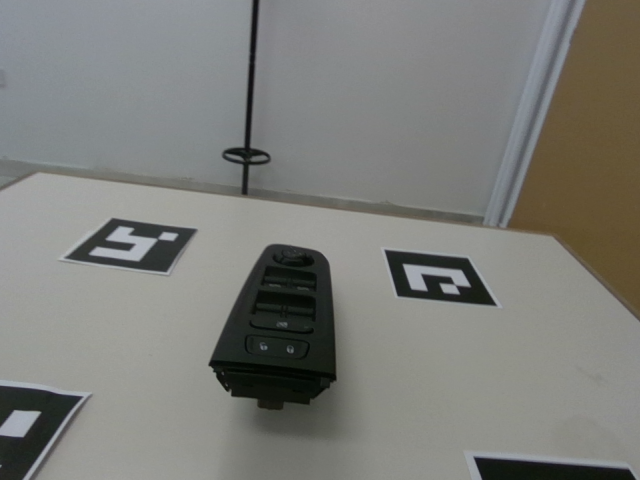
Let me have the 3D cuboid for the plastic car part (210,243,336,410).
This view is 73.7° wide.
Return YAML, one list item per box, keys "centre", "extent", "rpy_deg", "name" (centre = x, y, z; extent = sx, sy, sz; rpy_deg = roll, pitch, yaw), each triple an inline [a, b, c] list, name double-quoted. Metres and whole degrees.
- centre: [-0.022, 0.056, 0.319]
  extent: [0.066, 0.067, 0.203]
  rpy_deg: [-1, 23, 2]
  name: "plastic car part"
